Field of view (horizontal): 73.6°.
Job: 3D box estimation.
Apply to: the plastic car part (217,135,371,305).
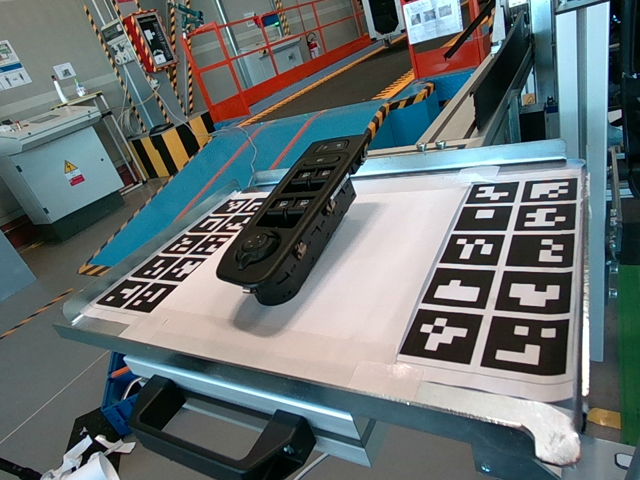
[{"bbox_3d":[-0.015,-0.019,0.371,0.067,0.067,0.202,7,40,27],"label":"plastic car part"}]
